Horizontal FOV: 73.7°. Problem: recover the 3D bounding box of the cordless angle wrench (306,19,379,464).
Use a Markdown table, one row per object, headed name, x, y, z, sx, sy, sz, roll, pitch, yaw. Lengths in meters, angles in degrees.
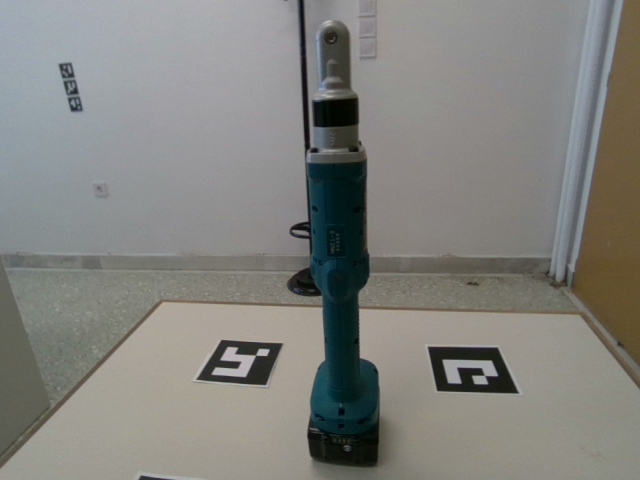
| name | x | y | z | sx | sy | sz | roll | pitch | yaw |
| --- | --- | --- | --- | --- | --- | --- | --- | --- | --- |
| cordless angle wrench | 0.019 | 0.024 | 0.410 | 0.074 | 0.422 | 0.097 | 0 | 20 | 9 |
